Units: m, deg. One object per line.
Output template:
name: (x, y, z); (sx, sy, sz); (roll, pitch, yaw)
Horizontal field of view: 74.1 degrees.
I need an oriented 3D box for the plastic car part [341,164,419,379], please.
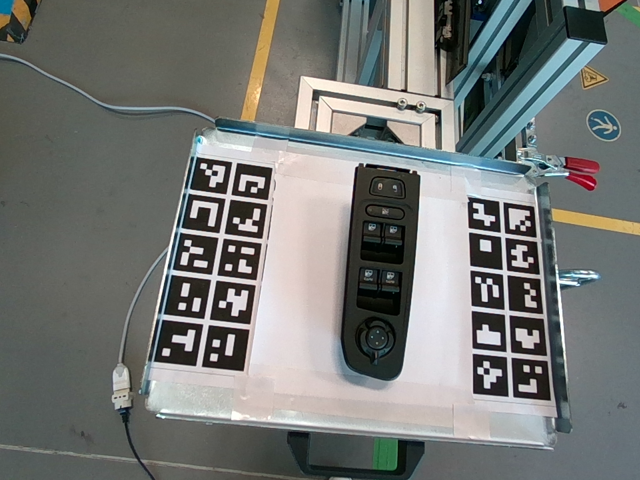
plastic car part: (0.052, 0.031, 0.424); (0.066, 0.202, 0.067); (8, -15, -13)
